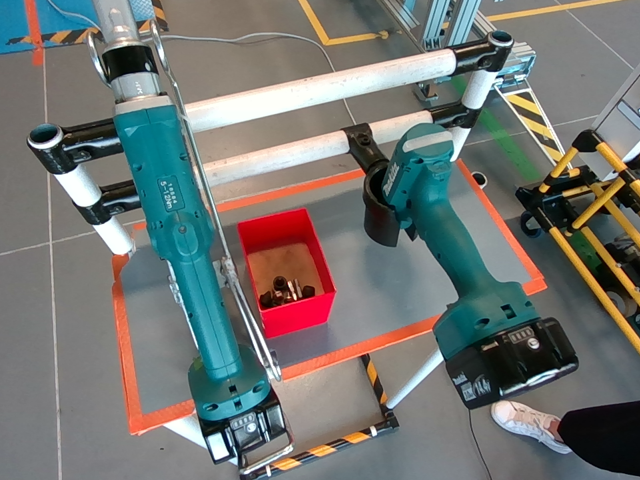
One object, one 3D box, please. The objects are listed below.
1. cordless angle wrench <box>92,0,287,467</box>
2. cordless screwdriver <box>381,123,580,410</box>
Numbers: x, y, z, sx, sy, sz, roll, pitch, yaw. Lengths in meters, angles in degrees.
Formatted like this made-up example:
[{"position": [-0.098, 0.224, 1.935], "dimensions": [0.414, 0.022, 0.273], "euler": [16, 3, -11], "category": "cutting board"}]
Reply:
[{"position": [-0.124, -0.008, 0.379], "dimensions": [0.074, 0.423, 0.098], "euler": [-18, 13, -19], "category": "cordless angle wrench"}, {"position": [0.124, 0.029, 0.414], "dimensions": [0.074, 0.248, 0.159], "euler": [-16, -22, -11], "category": "cordless screwdriver"}]
